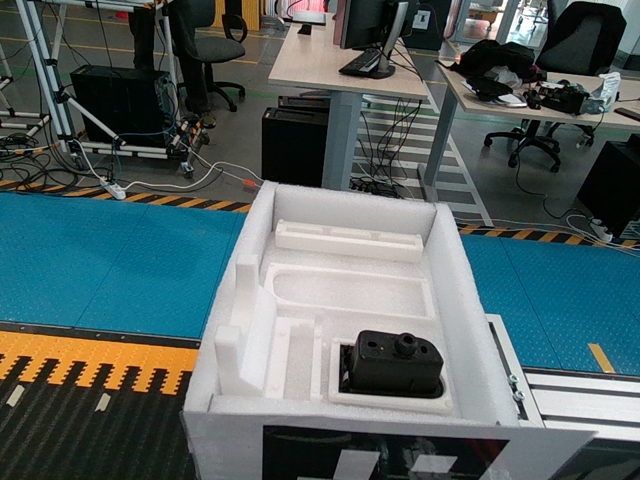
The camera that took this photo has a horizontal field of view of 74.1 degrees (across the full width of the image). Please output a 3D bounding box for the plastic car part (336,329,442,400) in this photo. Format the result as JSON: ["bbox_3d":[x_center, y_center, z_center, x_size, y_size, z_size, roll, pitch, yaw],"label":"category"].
[{"bbox_3d":[0.079,0.129,0.462,0.116,0.071,0.066,4,40,1],"label":"plastic car part"}]
